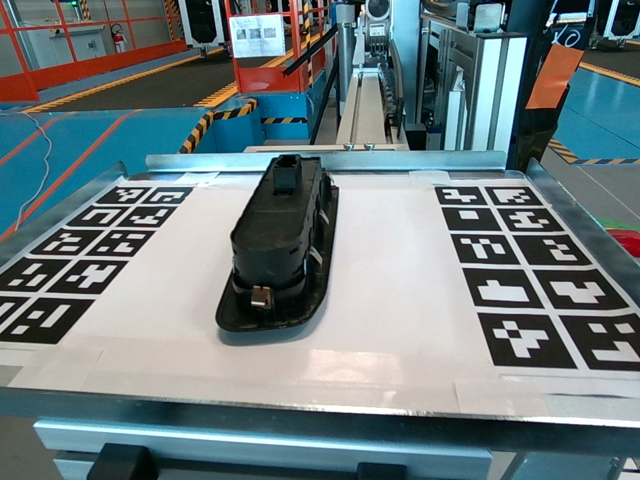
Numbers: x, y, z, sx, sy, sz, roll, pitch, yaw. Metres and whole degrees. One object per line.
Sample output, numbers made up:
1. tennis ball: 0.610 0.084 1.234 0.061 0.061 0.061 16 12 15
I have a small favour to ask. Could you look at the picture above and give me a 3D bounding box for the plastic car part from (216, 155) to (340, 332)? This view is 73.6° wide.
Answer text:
1. plastic car part: -0.020 -0.017 0.298 0.066 0.067 0.202 5 33 2
